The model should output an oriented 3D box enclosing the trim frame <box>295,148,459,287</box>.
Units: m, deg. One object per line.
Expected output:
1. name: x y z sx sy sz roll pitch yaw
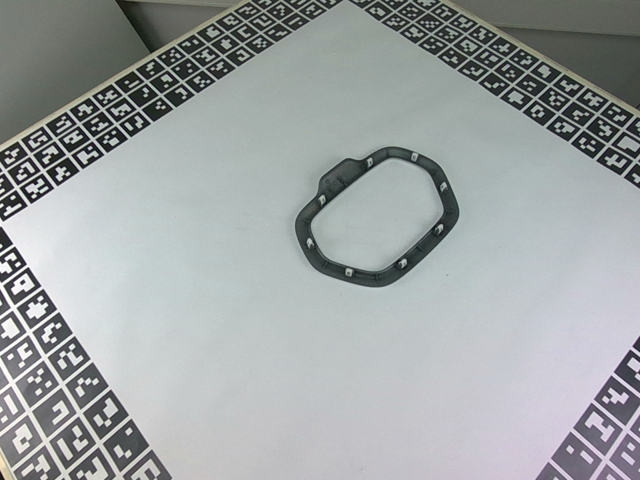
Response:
1. trim frame: 0.081 -0.040 0.598 0.247 0.184 0.027 -40 -23 -15
